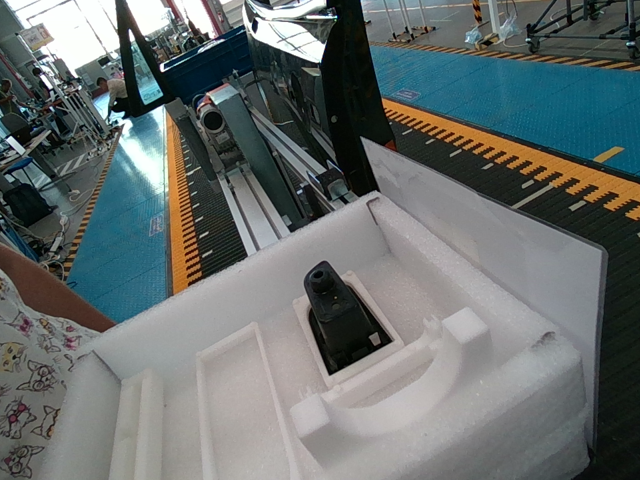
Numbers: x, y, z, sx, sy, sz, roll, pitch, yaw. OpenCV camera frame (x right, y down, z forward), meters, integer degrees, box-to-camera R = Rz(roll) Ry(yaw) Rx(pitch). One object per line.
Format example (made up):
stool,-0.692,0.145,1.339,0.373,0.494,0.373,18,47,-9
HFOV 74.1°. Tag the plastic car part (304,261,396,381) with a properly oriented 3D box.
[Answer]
plastic car part,0.013,0.064,0.415,0.066,0.071,0.116,-27,35,-4
